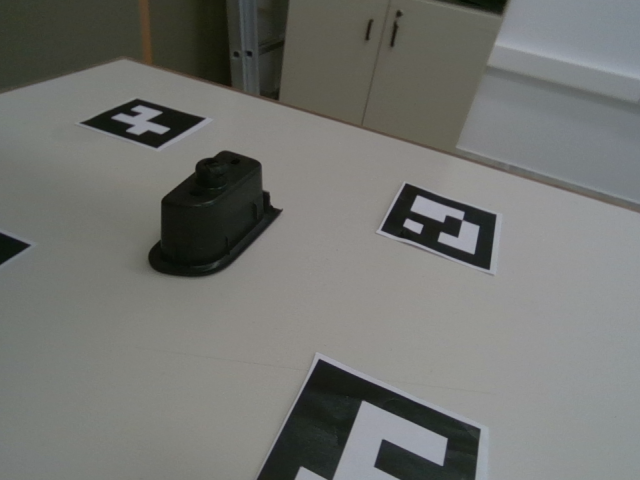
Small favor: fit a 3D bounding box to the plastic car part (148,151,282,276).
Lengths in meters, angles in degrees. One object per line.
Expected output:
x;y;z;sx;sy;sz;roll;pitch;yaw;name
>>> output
-0.080;-0.030;0.330;0.066;0.071;0.116;20;35;12;plastic car part
